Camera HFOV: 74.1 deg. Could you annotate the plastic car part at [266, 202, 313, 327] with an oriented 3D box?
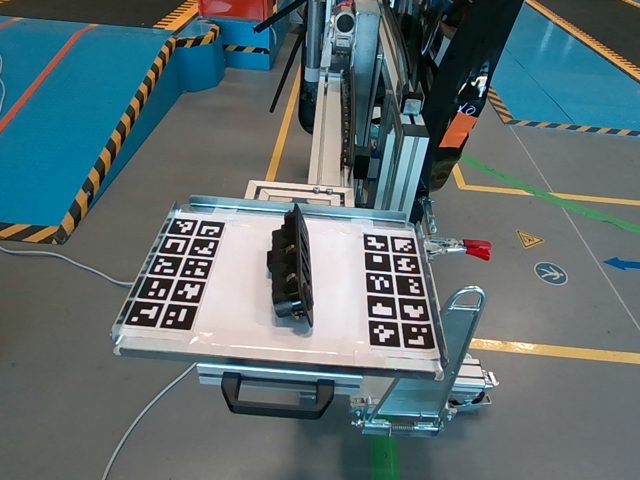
[{"bbox_3d":[-0.043,0.033,0.599,0.067,0.066,0.202,-11,42,-1],"label":"plastic car part"}]
